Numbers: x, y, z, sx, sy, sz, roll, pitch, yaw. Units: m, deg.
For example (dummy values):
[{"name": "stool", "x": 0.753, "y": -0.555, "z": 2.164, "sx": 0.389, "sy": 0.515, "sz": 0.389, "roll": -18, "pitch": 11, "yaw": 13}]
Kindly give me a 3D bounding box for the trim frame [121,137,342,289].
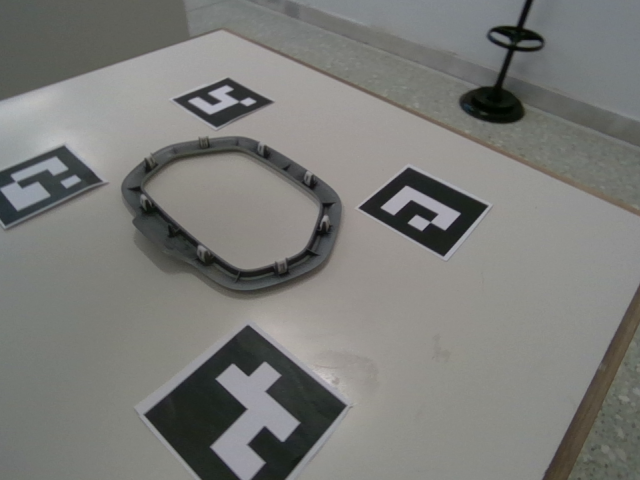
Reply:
[{"name": "trim frame", "x": -0.092, "y": -0.043, "z": 0.434, "sx": 0.250, "sy": 0.027, "sz": 0.183, "roll": 37, "pitch": 56, "yaw": 27}]
